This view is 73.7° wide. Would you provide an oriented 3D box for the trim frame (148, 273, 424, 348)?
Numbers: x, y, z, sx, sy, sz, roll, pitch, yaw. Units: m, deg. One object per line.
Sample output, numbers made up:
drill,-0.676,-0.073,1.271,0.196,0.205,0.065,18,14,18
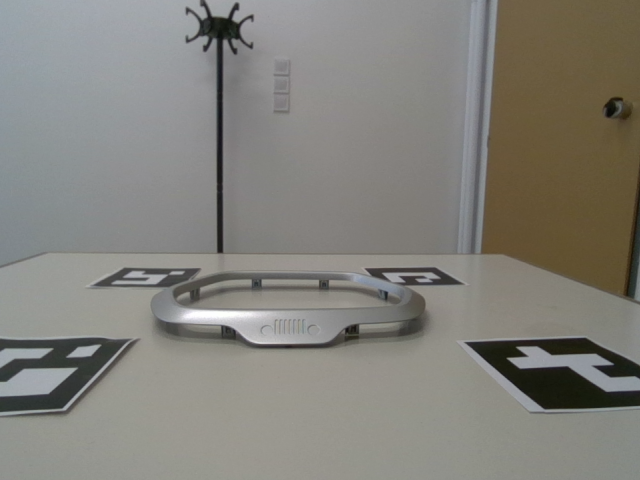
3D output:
trim frame,-0.030,0.057,0.395,0.248,0.027,0.184,2,7,-5
